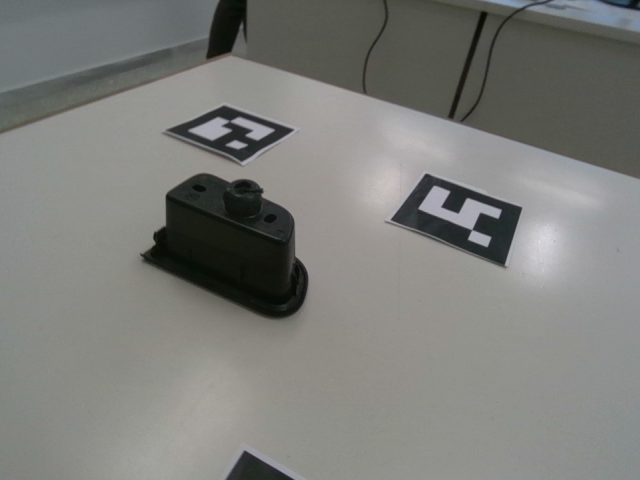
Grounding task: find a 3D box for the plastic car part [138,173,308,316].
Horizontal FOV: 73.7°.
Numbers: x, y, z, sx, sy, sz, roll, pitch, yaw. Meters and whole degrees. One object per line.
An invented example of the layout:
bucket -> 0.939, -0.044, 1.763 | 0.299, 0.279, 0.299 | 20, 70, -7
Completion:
plastic car part -> -0.057, -0.007, 0.283 | 0.117, 0.071, 0.065 | 20, 42, 18
